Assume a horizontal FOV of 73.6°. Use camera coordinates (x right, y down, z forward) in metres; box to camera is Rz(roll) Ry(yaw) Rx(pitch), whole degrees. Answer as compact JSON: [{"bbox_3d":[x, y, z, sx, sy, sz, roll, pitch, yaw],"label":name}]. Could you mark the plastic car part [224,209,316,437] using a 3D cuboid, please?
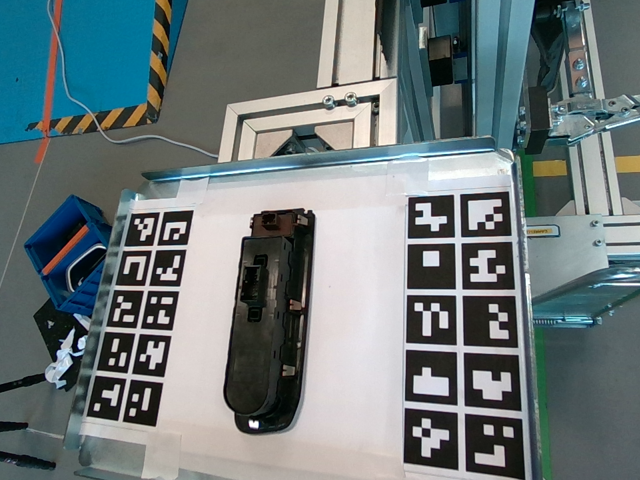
[{"bbox_3d":[-0.044,0.063,0.368,0.066,0.202,0.067,-1,-16,13],"label":"plastic car part"}]
